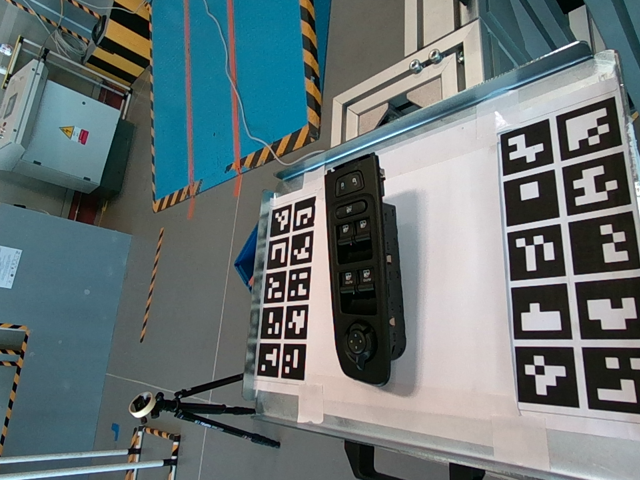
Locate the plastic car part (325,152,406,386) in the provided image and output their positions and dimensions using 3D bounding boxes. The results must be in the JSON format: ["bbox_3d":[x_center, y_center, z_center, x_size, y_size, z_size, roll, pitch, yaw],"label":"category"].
[{"bbox_3d":[0.045,0.028,0.400,0.067,0.202,0.067,-11,-18,37],"label":"plastic car part"}]
